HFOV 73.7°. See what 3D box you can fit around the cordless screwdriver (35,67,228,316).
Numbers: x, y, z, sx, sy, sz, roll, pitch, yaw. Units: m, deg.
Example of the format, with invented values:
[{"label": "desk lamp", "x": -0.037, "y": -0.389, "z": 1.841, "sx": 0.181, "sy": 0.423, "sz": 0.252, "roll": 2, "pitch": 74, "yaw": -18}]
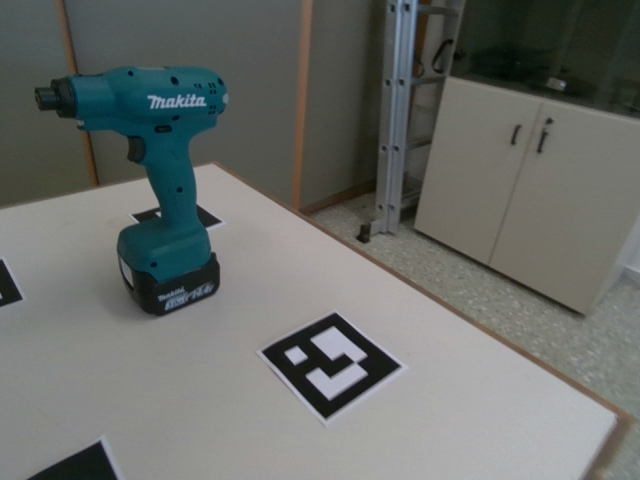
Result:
[{"label": "cordless screwdriver", "x": -0.175, "y": -0.042, "z": 0.429, "sx": 0.157, "sy": 0.249, "sz": 0.075, "roll": -17, "pitch": 36, "yaw": -38}]
